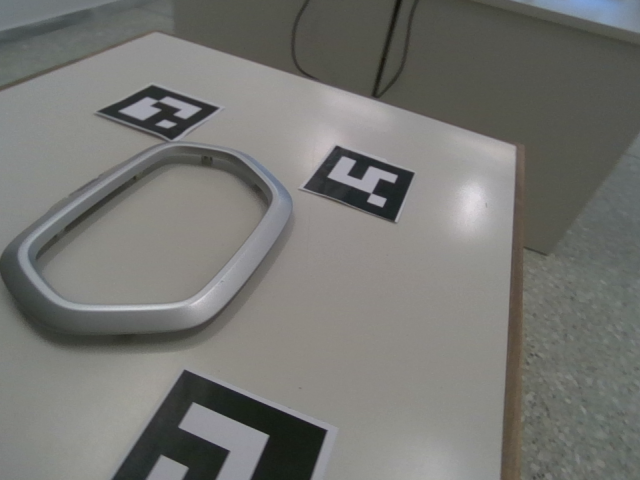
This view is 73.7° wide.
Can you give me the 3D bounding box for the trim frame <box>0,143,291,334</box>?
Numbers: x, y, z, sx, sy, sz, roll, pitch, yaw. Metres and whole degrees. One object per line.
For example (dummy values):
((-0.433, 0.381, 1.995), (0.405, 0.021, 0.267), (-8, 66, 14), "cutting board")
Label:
((-0.130, -0.017, 0.358), (0.185, 0.027, 0.247), (20, 44, 9), "trim frame")
